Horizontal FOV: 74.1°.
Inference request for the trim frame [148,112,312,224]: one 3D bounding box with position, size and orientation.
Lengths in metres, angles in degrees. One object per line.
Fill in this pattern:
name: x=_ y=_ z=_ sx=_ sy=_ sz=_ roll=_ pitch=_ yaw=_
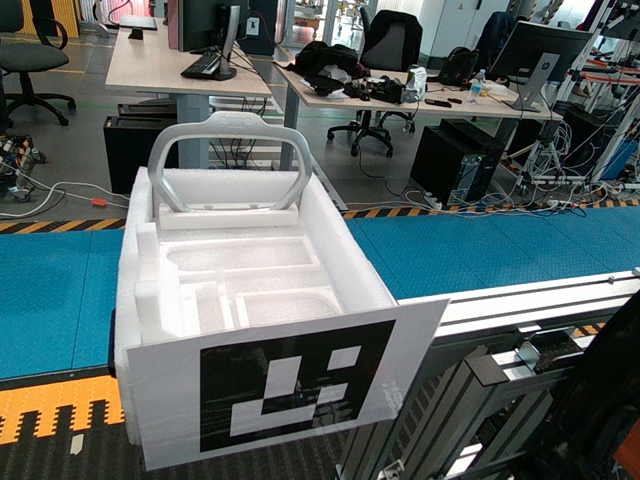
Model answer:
trim frame: x=-0.131 y=-0.103 z=0.652 sx=0.248 sy=0.184 sz=0.027 roll=-3 pitch=38 yaw=-16
